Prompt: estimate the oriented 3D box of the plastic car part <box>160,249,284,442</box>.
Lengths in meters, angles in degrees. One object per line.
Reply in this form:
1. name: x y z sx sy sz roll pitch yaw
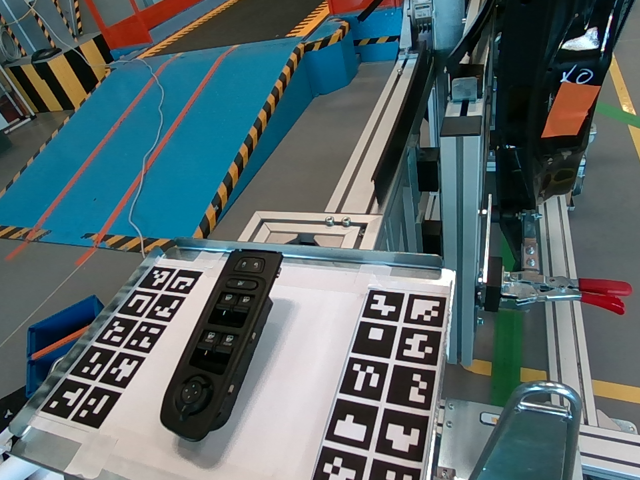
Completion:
1. plastic car part: -0.094 0.103 0.437 0.066 0.202 0.067 8 -41 15
